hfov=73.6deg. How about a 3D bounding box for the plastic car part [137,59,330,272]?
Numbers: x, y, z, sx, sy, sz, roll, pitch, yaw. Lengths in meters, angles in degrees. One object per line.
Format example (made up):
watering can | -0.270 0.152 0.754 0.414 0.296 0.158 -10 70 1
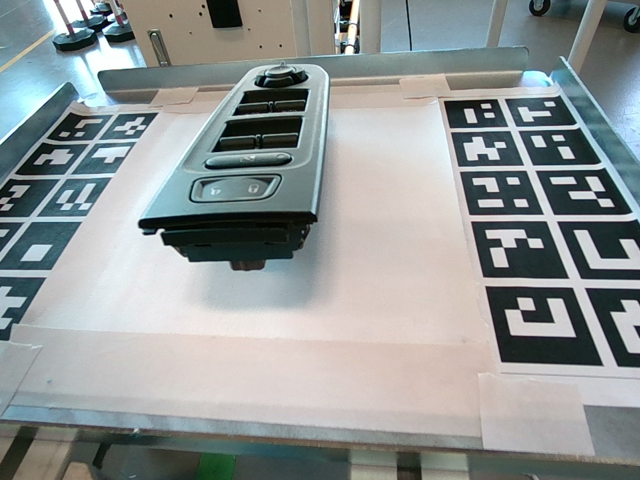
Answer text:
plastic car part | -0.025 -0.051 0.241 0.066 0.067 0.202 -7 42 10
